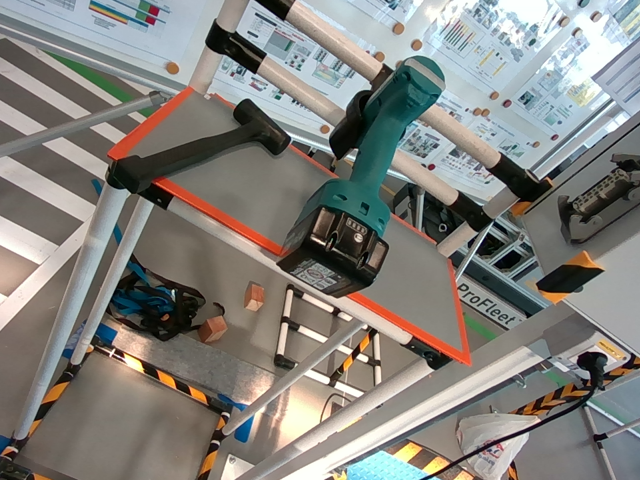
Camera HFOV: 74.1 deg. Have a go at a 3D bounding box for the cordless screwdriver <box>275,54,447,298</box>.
[{"bbox_3d":[0.037,-0.064,0.449,0.074,0.248,0.160,31,-22,-13],"label":"cordless screwdriver"}]
